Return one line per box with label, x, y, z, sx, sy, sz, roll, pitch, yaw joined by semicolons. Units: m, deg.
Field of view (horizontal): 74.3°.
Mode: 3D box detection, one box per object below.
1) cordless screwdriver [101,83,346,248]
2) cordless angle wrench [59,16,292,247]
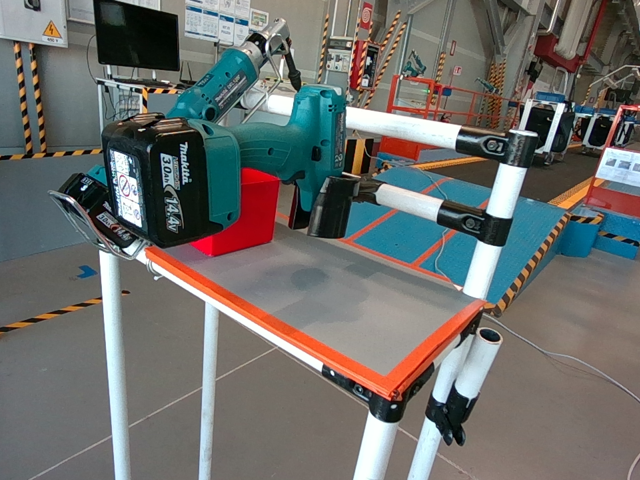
cordless screwdriver;-0.064;-0.057;0.407;0.074;0.159;0.248;22;34;36
cordless angle wrench;-0.173;-0.181;0.601;0.074;0.422;0.098;27;-20;28
